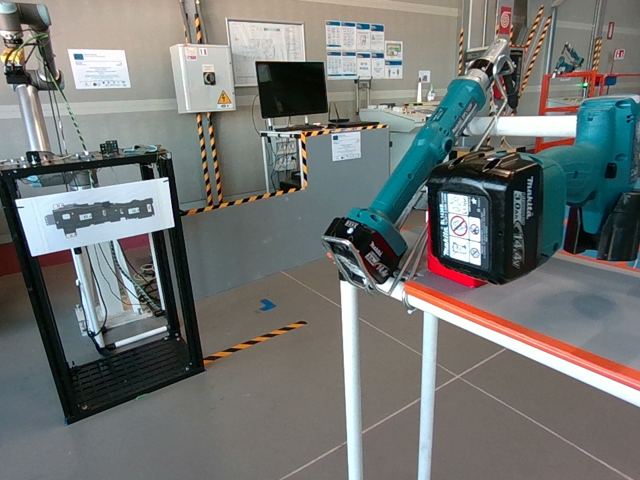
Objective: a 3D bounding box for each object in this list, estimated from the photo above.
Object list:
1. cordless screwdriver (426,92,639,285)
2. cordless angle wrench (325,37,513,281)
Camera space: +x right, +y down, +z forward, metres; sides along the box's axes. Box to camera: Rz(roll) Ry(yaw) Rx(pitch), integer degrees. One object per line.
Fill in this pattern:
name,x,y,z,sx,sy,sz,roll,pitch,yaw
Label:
cordless screwdriver,0.211,-0.030,0.386,0.248,0.159,0.074,-24,24,-27
cordless angle wrench,0.167,-0.138,0.621,0.074,0.422,0.098,26,-13,48
